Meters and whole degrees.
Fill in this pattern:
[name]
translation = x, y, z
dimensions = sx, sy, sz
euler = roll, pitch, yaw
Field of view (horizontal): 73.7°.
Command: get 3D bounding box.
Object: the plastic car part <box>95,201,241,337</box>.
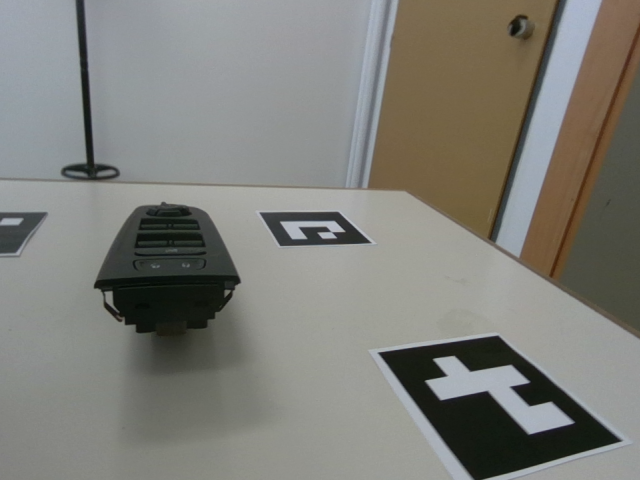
[plastic car part]
translation = -0.100, 0.014, 0.297
dimensions = 0.066, 0.067, 0.204
euler = -8, 22, -16
